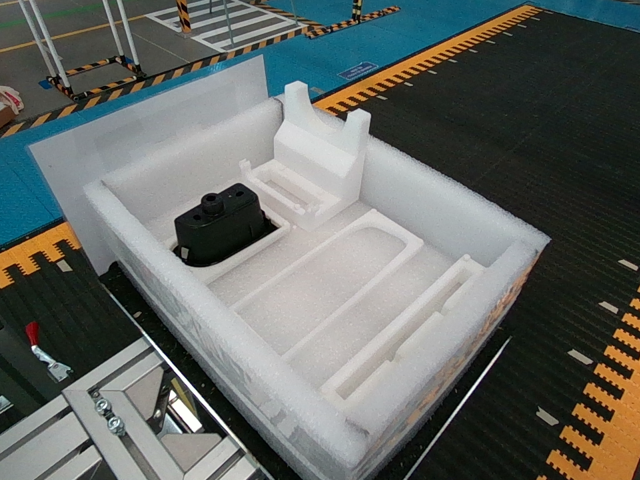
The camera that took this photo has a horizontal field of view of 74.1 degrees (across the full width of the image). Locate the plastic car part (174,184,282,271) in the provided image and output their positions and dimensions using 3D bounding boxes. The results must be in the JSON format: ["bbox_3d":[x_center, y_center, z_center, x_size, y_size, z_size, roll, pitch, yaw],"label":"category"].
[{"bbox_3d":[-0.108,-0.021,0.470,0.116,0.071,0.066,-32,52,-32],"label":"plastic car part"}]
